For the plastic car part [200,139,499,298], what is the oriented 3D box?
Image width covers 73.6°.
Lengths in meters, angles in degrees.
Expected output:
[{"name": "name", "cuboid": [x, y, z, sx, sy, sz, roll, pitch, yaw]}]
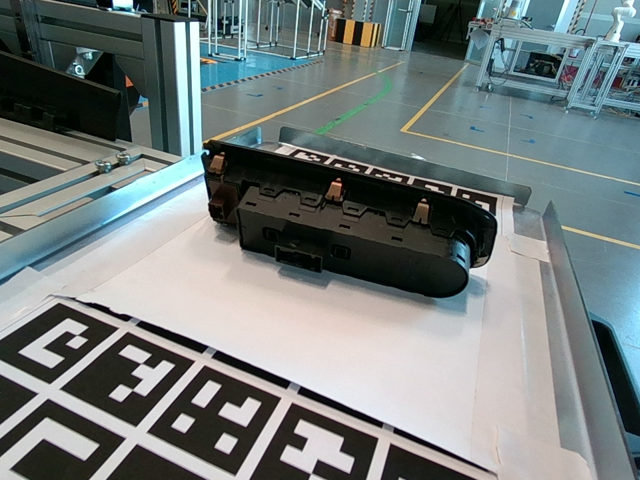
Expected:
[{"name": "plastic car part", "cuboid": [0.013, -0.009, 0.277, 0.203, 0.066, 0.067, 11, 42, 7]}]
